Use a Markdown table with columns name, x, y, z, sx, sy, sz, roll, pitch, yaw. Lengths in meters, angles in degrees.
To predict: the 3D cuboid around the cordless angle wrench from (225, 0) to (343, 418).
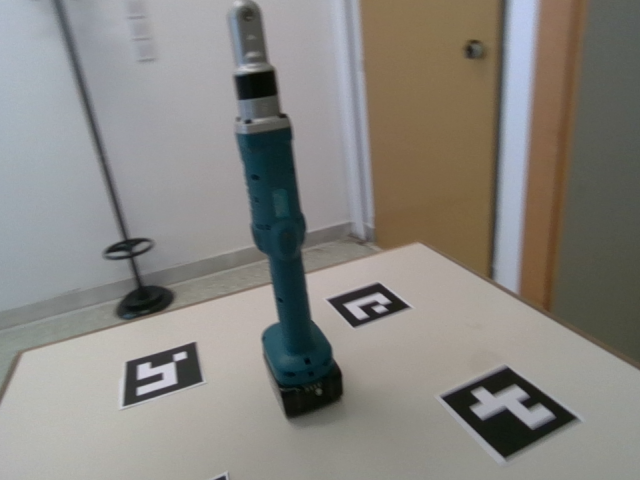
| name | x | y | z | sx | sy | sz | roll | pitch | yaw |
| --- | --- | --- | --- | --- | --- | --- | --- | --- | --- |
| cordless angle wrench | -0.044 | -0.011 | 0.443 | 0.074 | 0.422 | 0.098 | -14 | 23 | -17 |
